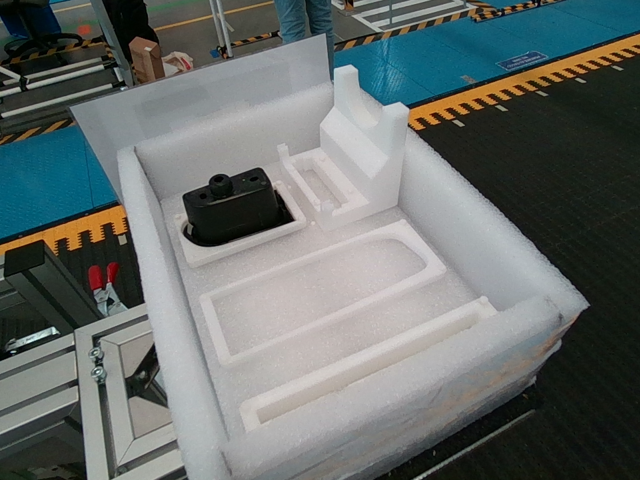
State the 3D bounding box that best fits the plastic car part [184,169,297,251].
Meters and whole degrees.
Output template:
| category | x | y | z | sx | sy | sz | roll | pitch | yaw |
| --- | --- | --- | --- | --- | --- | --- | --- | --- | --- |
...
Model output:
| category | x | y | z | sx | sy | sz | roll | pitch | yaw |
| --- | --- | --- | --- | --- | --- | --- | --- | --- | --- |
| plastic car part | -0.092 | -0.039 | 0.456 | 0.116 | 0.071 | 0.066 | -18 | 46 | -14 |
